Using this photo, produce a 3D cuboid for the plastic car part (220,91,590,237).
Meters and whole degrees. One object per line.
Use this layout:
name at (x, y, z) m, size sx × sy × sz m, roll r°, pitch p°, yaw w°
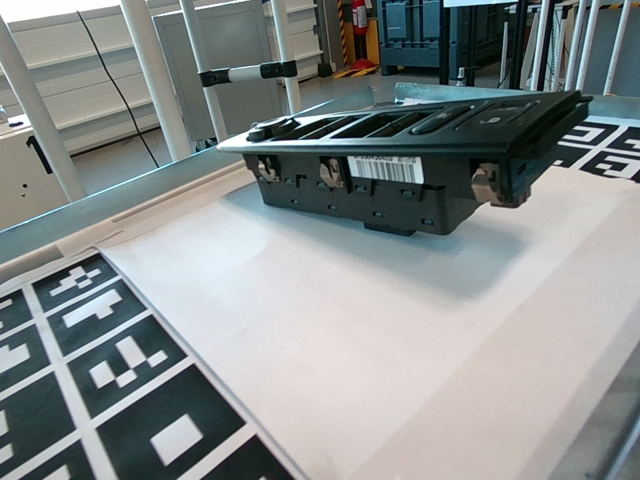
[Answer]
plastic car part at (0.021, -0.041, 0.230) m, size 0.204 × 0.067 × 0.066 m, roll 18°, pitch 51°, yaw 44°
